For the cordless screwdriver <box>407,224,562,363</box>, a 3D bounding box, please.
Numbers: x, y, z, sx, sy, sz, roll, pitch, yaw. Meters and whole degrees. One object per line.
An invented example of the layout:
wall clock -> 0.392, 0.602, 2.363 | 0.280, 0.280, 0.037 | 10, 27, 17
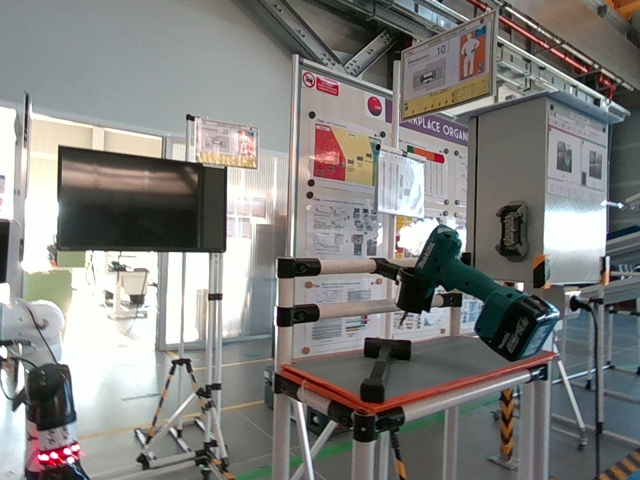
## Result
cordless screwdriver -> 0.247, 0.101, 0.700 | 0.074, 0.159, 0.248 | 1, 32, -35
